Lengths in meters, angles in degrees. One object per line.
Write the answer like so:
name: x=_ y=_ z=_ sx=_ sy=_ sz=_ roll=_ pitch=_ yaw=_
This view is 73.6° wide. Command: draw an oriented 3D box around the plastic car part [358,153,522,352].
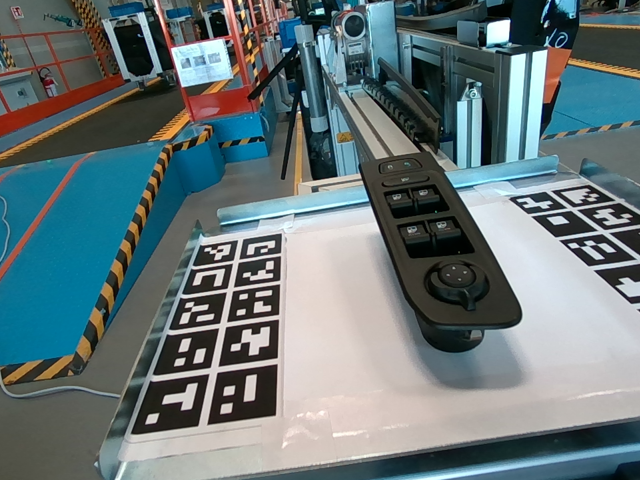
plastic car part: x=0.076 y=0.004 z=0.318 sx=0.066 sy=0.067 sz=0.202 roll=-3 pitch=33 yaw=-4
